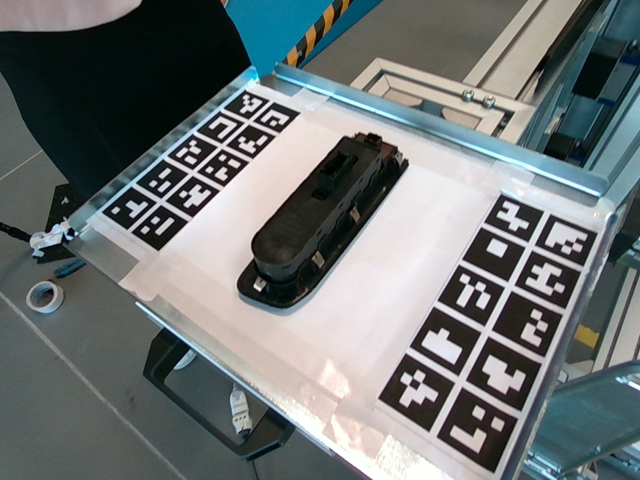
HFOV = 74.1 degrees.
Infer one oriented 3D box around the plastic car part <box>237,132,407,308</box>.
[{"bbox_3d":[0.006,-0.029,0.367,0.066,0.202,0.067,31,-23,14],"label":"plastic car part"}]
